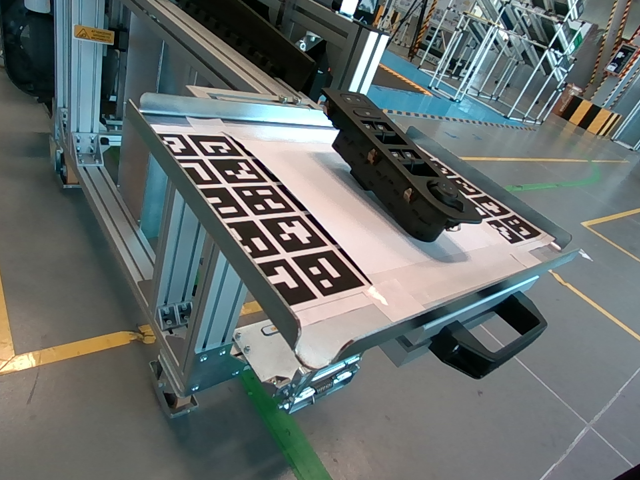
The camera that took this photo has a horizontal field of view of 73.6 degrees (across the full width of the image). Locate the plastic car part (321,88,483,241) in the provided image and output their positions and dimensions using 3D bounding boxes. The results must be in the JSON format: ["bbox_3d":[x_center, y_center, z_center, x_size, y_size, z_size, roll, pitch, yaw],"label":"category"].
[{"bbox_3d":[0.067,-0.072,0.420,0.066,0.067,0.203,-2,43,-47],"label":"plastic car part"}]
